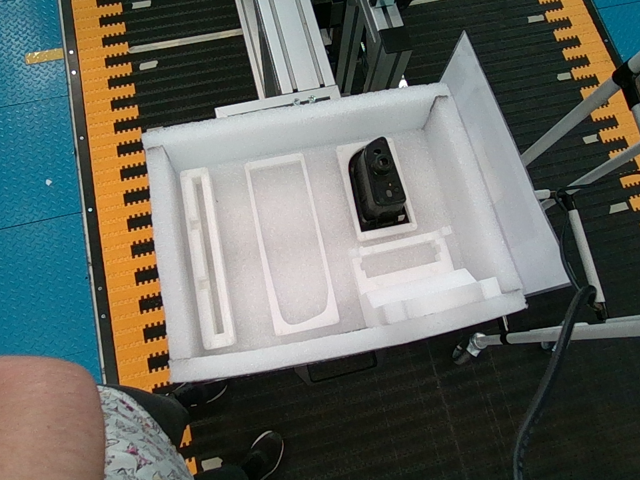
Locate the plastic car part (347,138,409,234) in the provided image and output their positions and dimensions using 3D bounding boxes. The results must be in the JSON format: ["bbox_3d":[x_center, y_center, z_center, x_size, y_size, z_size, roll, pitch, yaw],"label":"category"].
[{"bbox_3d":[0.073,-0.076,0.532,0.066,0.116,0.071,-11,-12,-8],"label":"plastic car part"}]
